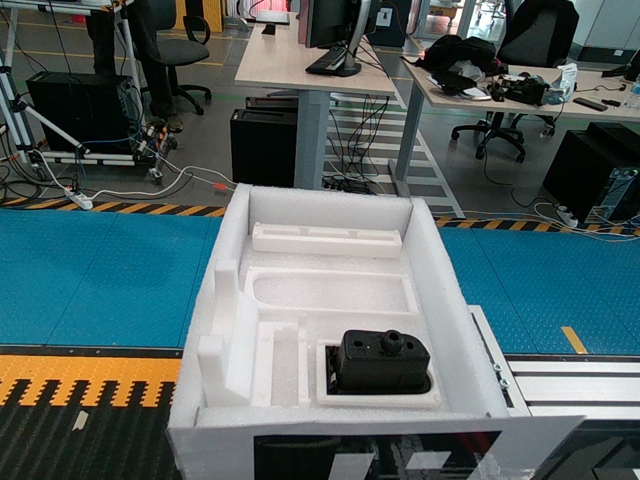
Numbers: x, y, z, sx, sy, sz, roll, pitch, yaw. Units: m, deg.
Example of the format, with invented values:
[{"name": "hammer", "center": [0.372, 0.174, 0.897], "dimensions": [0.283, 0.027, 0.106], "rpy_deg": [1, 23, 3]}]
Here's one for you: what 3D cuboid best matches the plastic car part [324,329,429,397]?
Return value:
[{"name": "plastic car part", "center": [0.064, 0.126, 0.459], "dimensions": [0.116, 0.071, 0.066], "rpy_deg": [2, 39, -2]}]
